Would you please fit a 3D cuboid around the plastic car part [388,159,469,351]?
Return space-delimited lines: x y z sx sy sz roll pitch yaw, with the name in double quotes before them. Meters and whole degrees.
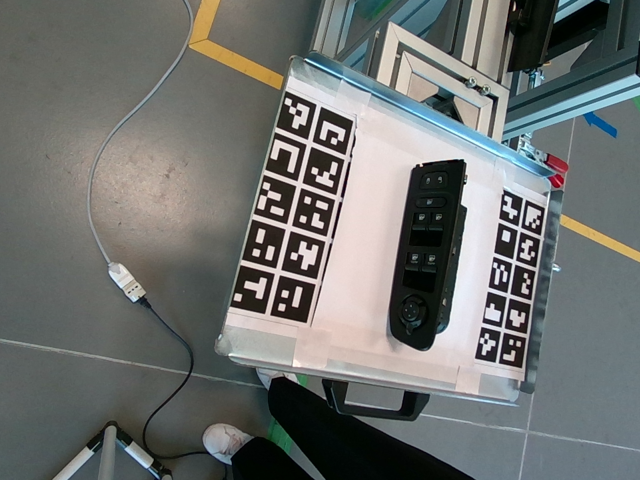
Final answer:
"plastic car part" 0.122 0.018 0.469 0.067 0.203 0.067 6 -13 38
